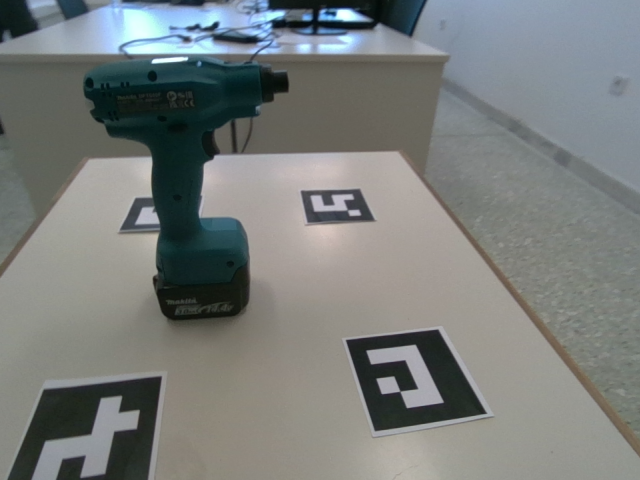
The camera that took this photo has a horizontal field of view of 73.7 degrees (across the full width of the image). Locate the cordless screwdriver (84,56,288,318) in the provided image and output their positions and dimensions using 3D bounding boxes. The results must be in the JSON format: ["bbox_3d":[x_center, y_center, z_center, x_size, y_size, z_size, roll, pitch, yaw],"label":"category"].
[{"bbox_3d":[-0.103,-0.042,0.408,0.159,0.248,0.074,-5,34,-5],"label":"cordless screwdriver"}]
